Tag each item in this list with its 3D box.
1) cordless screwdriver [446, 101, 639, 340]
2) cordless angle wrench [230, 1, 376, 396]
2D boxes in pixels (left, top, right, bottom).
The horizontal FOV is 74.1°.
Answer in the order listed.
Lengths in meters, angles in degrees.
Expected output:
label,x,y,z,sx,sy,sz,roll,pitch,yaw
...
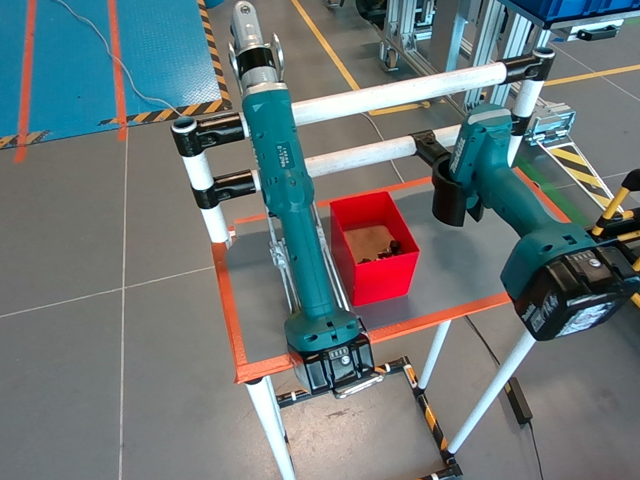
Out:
label,x,y,z,sx,sy,sz,roll,pitch,yaw
cordless screwdriver,0.211,-0.014,0.469,0.074,0.248,0.159,-13,-32,-7
cordless angle wrench,-0.035,-0.053,0.463,0.074,0.422,0.098,-14,0,-14
